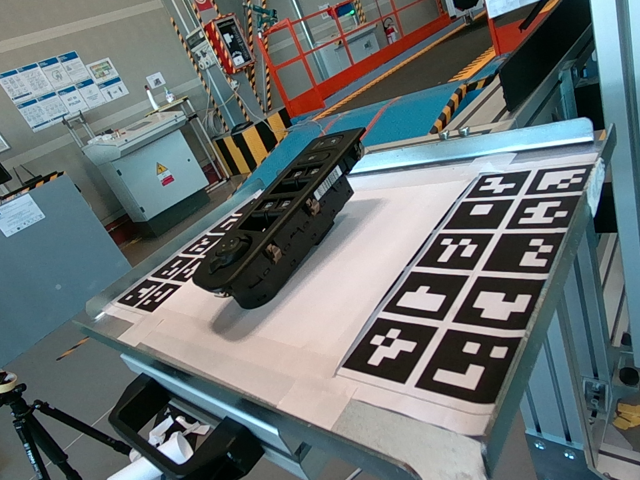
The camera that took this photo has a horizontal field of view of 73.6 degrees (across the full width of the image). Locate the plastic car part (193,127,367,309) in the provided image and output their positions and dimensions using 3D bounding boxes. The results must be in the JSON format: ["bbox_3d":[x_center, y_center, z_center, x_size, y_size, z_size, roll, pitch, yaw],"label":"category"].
[{"bbox_3d":[-0.025,-0.018,0.364,0.067,0.067,0.202,8,43,39],"label":"plastic car part"}]
